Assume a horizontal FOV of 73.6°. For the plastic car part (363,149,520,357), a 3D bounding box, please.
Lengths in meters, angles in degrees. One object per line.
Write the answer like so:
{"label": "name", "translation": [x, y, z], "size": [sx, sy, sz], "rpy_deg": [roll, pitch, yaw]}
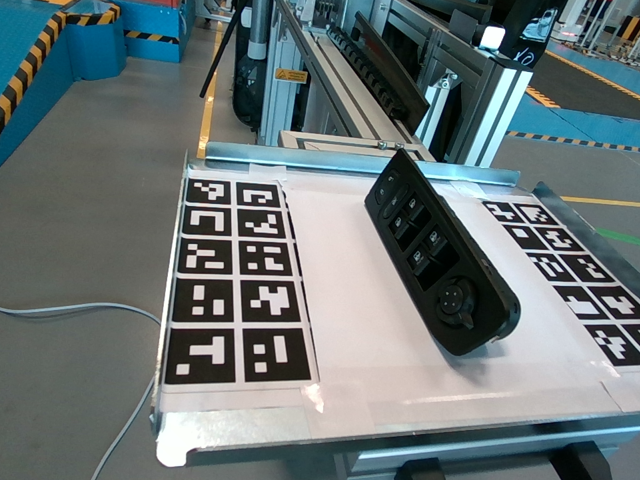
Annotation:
{"label": "plastic car part", "translation": [0.096, 0.009, 0.350], "size": [0.067, 0.067, 0.203], "rpy_deg": [27, 29, -28]}
